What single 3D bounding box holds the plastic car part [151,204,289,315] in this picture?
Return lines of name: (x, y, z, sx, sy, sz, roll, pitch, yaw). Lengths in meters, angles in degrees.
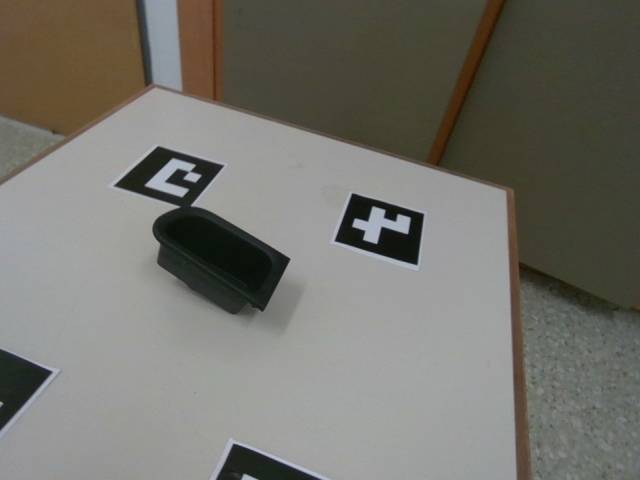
plastic car part: (-0.100, 0.023, 0.389, 0.116, 0.066, 0.071, 33, -44, -8)
